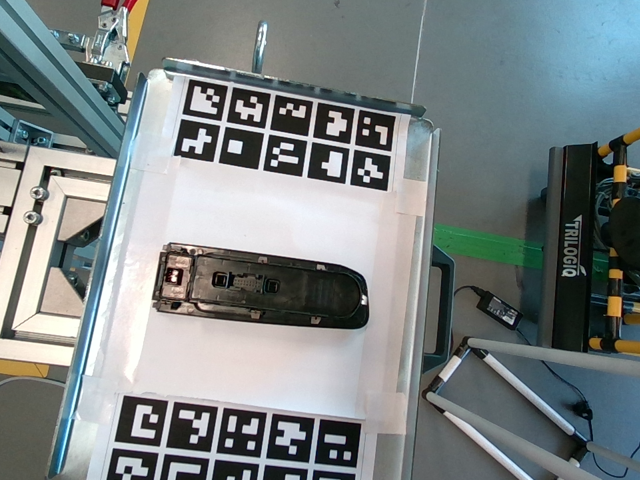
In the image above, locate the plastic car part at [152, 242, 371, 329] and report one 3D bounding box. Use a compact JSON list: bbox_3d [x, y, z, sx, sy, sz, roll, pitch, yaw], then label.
[{"bbox_3d":[-0.047,0.041,0.387,0.203,0.066,0.067,8,-16,-8],"label":"plastic car part"}]
